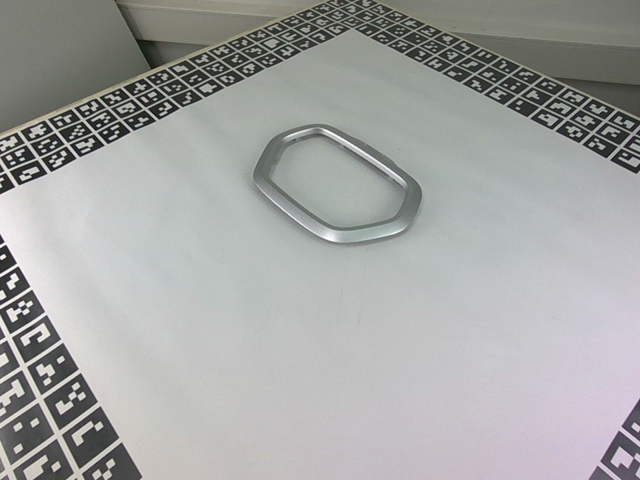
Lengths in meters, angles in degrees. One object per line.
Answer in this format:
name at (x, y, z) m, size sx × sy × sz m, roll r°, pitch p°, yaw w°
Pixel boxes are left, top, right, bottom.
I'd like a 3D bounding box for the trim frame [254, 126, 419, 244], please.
trim frame at (0.021, -0.085, 0.601) m, size 0.249 × 0.027 × 0.183 m, roll 38°, pitch 62°, yaw 26°
